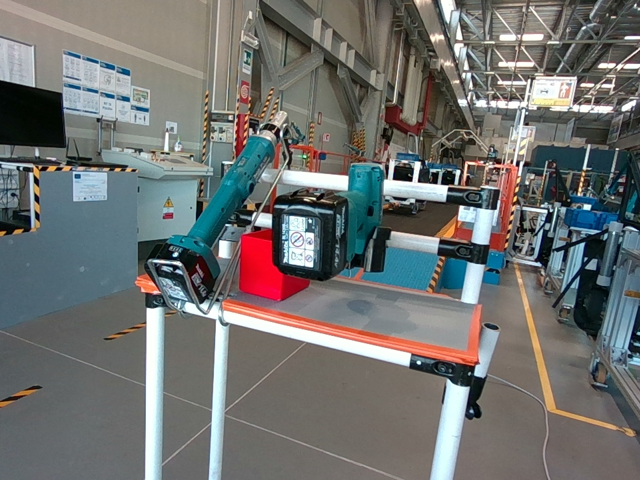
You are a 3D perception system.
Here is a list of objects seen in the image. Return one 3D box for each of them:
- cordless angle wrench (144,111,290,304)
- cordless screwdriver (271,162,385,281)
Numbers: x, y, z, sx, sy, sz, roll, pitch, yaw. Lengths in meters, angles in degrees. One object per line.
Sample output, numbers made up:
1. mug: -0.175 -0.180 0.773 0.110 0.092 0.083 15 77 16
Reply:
1. cordless angle wrench: -0.143 -0.091 0.730 0.074 0.421 0.098 13 -35 16
2. cordless screwdriver: 0.029 -0.009 0.554 0.074 0.159 0.248 7 19 23
